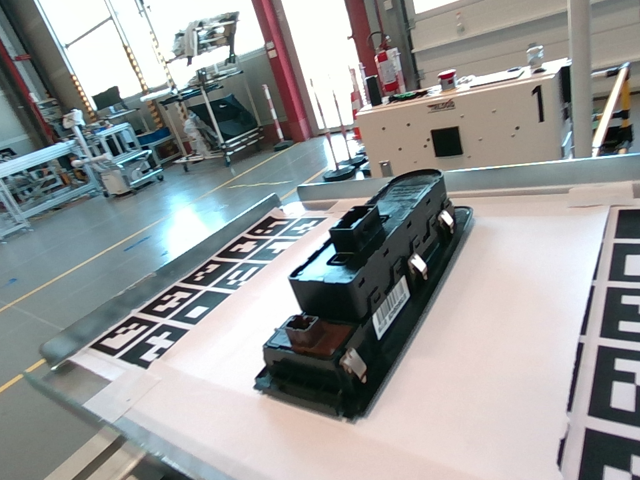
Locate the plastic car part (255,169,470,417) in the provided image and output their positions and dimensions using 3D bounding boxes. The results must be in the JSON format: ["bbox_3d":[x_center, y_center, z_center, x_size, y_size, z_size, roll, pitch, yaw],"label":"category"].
[{"bbox_3d":[0.036,0.007,0.263,0.067,0.067,0.201,-7,22,39],"label":"plastic car part"}]
